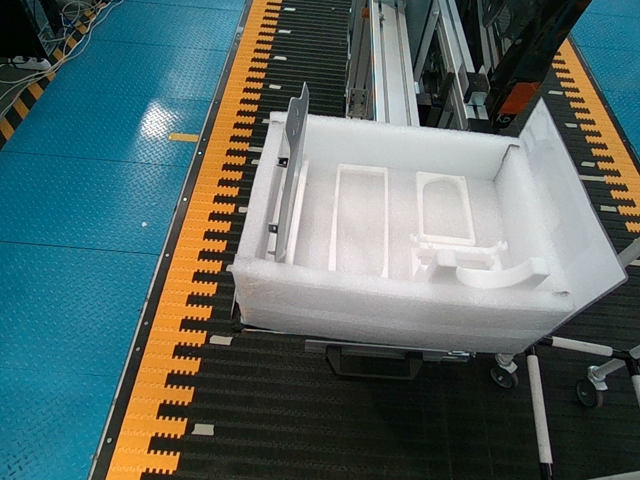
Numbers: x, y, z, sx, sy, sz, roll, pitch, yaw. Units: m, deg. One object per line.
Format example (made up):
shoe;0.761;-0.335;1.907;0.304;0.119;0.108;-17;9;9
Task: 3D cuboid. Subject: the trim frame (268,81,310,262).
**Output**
trim frame;-0.038;-0.085;0.537;0.027;0.247;0.185;11;-33;-2
